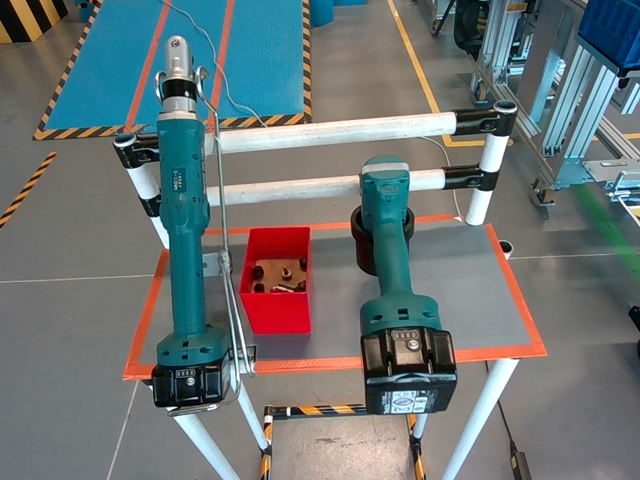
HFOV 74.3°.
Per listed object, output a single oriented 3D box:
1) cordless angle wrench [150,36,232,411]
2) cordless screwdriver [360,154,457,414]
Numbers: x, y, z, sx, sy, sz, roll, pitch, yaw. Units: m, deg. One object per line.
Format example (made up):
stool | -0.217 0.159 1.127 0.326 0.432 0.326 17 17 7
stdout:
cordless angle wrench | -0.155 -0.030 0.491 0.074 0.422 0.098 -4 -3 -4
cordless screwdriver | 0.076 0.050 0.443 0.074 0.248 0.159 -4 -35 5
